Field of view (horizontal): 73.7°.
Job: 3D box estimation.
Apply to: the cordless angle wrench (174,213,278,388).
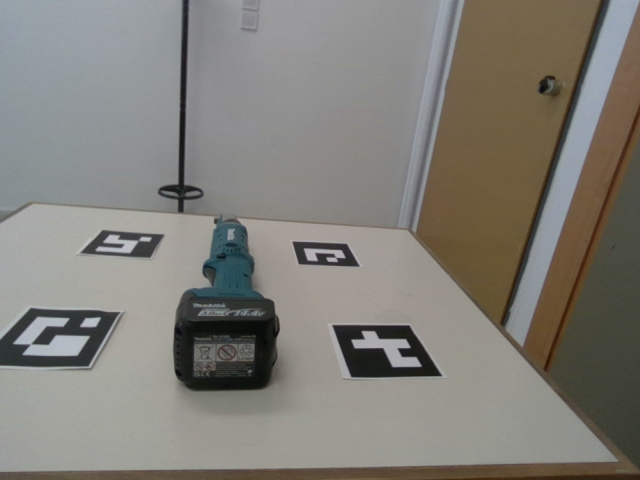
[{"bbox_3d":[-0.125,0.034,0.585,0.097,0.074,0.424,2,20,-12],"label":"cordless angle wrench"}]
